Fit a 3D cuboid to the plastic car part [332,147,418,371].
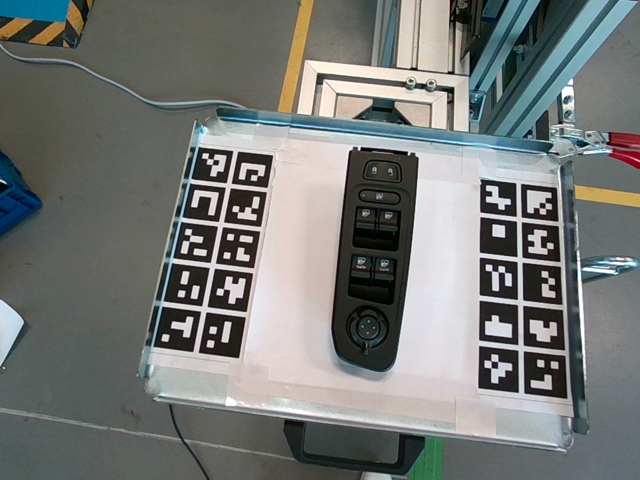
[{"bbox_3d":[0.047,0.018,0.408,0.066,0.202,0.067,8,-13,-6],"label":"plastic car part"}]
